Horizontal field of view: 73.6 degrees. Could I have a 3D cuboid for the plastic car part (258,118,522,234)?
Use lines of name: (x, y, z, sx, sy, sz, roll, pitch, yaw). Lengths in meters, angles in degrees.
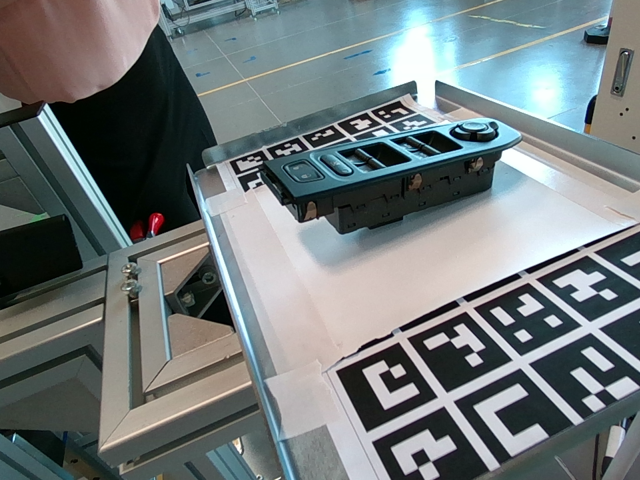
plastic car part: (0.063, -0.048, 0.323, 0.202, 0.067, 0.066, -20, 30, -15)
